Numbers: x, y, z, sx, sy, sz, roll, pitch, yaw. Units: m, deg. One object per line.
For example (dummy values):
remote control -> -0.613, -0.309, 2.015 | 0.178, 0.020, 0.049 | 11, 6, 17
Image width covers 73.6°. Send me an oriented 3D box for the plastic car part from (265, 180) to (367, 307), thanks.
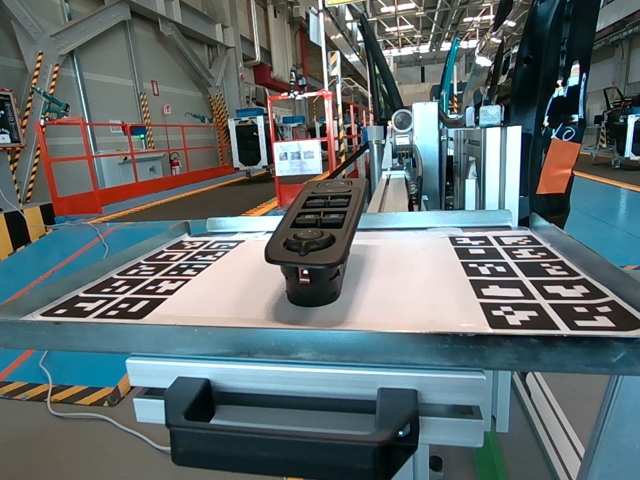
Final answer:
plastic car part -> 0.001, -0.004, 0.369 | 0.066, 0.067, 0.202 | 6, 19, 7
